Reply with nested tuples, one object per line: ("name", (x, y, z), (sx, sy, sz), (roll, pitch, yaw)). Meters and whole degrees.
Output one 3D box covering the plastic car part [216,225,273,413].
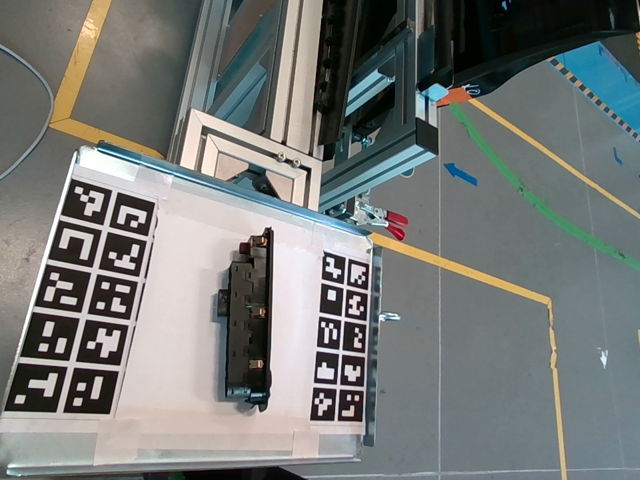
("plastic car part", (-0.079, 0.088, 0.470), (0.067, 0.202, 0.067), (1, -12, -23))
